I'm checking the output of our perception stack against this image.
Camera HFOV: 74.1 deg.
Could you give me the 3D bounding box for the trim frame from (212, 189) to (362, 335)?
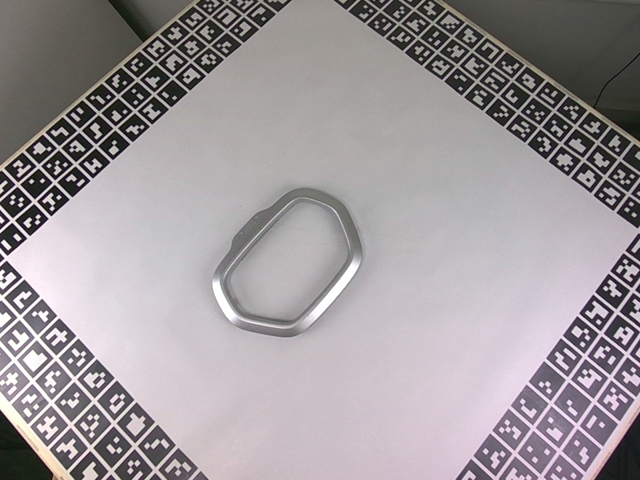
[{"bbox_3d":[-0.048,0.029,0.644,0.184,0.248,0.027,38,-14,13],"label":"trim frame"}]
